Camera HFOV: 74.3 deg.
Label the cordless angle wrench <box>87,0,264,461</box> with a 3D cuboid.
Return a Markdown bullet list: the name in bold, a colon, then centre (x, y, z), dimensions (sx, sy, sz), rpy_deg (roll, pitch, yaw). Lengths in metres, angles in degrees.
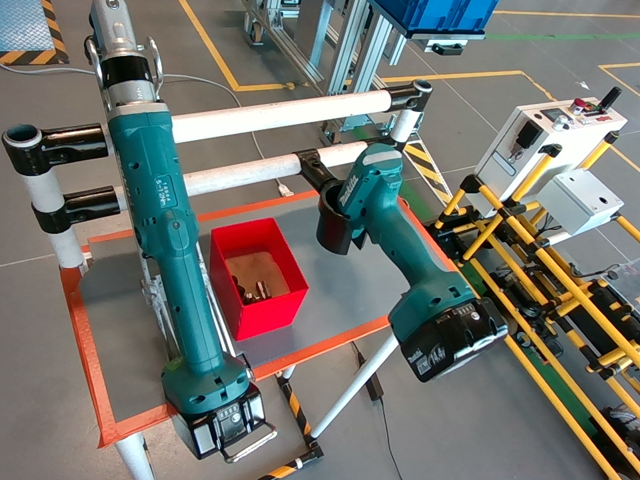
- **cordless angle wrench**: centre (-0.144, -0.009, 0.397), dimensions (0.074, 0.423, 0.098), rpy_deg (-19, 13, -36)

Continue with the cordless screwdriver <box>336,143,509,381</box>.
- **cordless screwdriver**: centre (0.088, 0.031, 0.485), dimensions (0.074, 0.248, 0.160), rpy_deg (-15, -24, -24)
